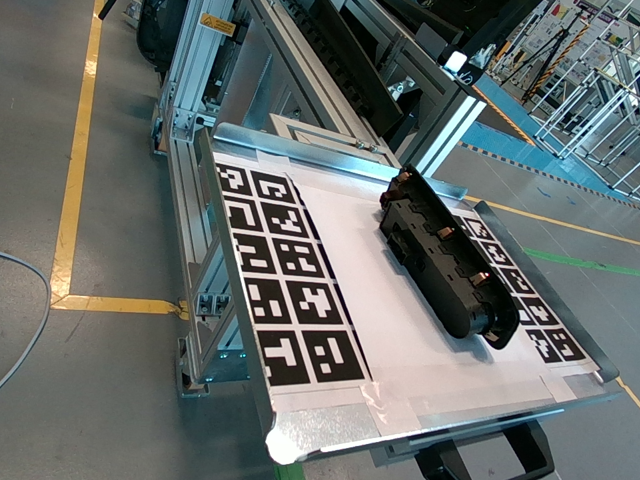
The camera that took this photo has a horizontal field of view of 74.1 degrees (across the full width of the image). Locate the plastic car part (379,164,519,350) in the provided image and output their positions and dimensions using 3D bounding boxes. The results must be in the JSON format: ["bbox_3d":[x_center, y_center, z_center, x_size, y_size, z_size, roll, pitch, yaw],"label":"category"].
[{"bbox_3d":[0.111,0.015,0.414,0.067,0.203,0.066,-11,-36,-31],"label":"plastic car part"}]
